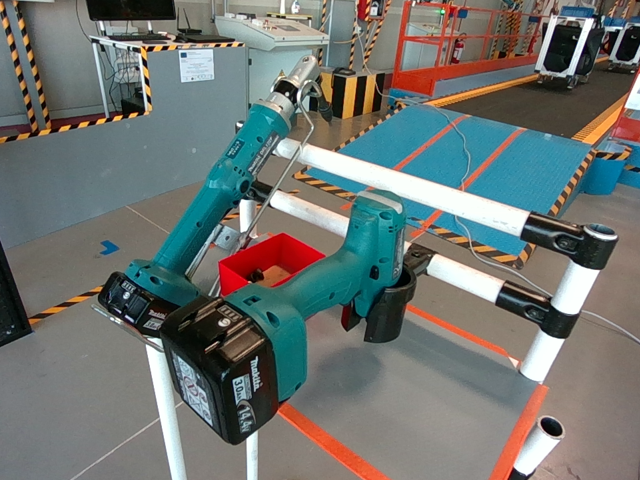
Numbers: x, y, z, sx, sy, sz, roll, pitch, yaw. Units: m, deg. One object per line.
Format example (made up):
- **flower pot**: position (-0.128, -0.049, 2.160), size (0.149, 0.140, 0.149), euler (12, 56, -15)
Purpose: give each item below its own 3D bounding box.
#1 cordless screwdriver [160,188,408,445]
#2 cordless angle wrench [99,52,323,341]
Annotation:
- **cordless screwdriver**: position (-0.007, 0.070, 0.383), size (0.074, 0.159, 0.248), euler (27, 46, 34)
- **cordless angle wrench**: position (-0.116, -0.075, 0.551), size (0.074, 0.422, 0.098), euler (27, -10, 28)
